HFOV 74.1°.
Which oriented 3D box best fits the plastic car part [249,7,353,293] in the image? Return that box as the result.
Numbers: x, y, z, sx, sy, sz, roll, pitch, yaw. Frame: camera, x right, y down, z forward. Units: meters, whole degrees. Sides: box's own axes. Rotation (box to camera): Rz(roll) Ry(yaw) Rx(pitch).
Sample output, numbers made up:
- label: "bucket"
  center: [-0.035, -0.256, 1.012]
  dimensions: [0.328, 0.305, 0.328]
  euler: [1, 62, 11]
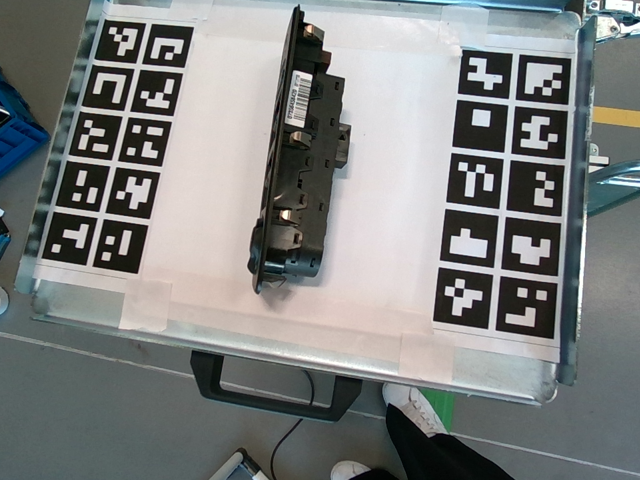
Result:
- label: "plastic car part"
  center: [-0.014, -0.058, 0.317]
  dimensions: [0.067, 0.203, 0.067]
  euler: [15, -12, -19]
